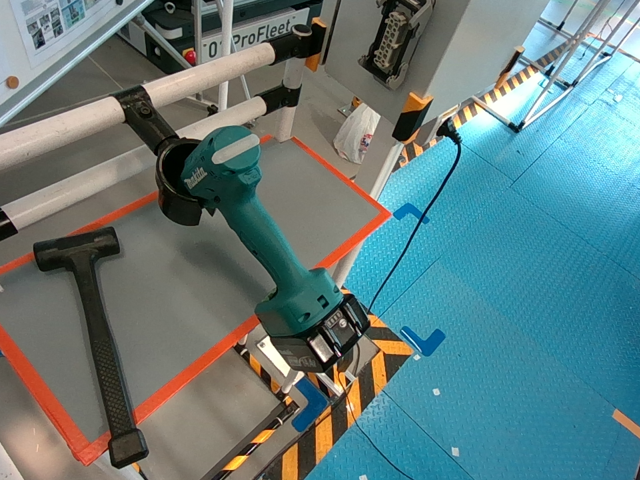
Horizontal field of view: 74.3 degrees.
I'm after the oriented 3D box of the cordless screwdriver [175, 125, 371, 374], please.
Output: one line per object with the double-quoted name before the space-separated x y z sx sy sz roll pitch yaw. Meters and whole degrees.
"cordless screwdriver" -0.063 0.017 0.440 0.074 0.249 0.159 -38 13 -33
